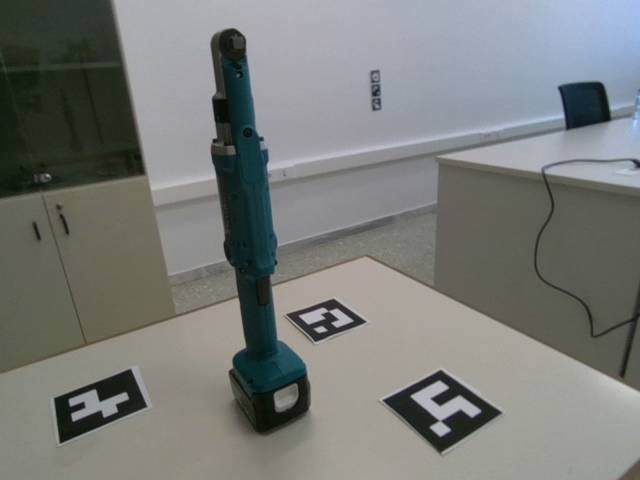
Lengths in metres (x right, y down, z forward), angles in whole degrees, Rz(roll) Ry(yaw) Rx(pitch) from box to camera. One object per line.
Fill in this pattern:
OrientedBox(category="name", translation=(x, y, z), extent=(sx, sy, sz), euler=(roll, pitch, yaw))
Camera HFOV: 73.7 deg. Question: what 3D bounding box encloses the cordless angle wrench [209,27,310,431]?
OrientedBox(category="cordless angle wrench", translation=(-0.074, 0.008, 0.458), extent=(0.074, 0.422, 0.099), euler=(-16, 24, -29))
